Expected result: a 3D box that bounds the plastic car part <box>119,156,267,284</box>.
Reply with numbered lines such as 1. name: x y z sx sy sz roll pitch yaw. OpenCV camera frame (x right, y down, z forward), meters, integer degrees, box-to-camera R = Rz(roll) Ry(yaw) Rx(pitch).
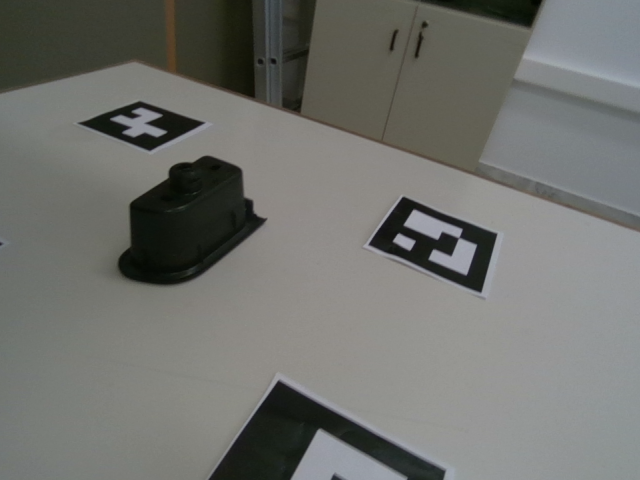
1. plastic car part: -0.094 -0.025 0.319 0.066 0.071 0.115 22 35 15
